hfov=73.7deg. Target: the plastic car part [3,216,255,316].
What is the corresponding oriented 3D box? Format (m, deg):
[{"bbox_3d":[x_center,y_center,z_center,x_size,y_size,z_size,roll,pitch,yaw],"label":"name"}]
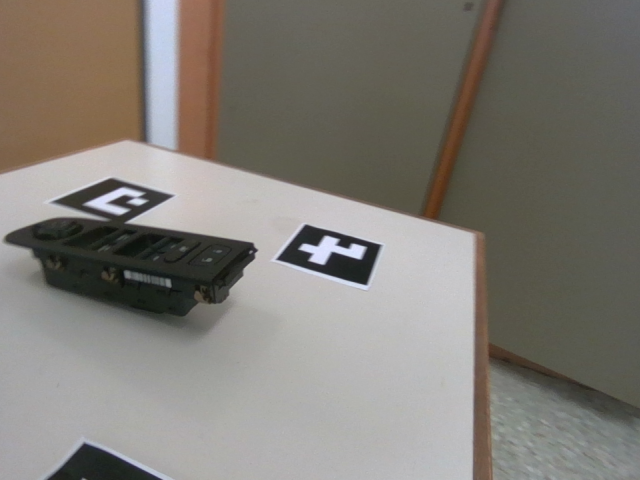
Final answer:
[{"bbox_3d":[-0.156,0.019,0.347,0.204,0.067,0.066,12,37,14],"label":"plastic car part"}]
